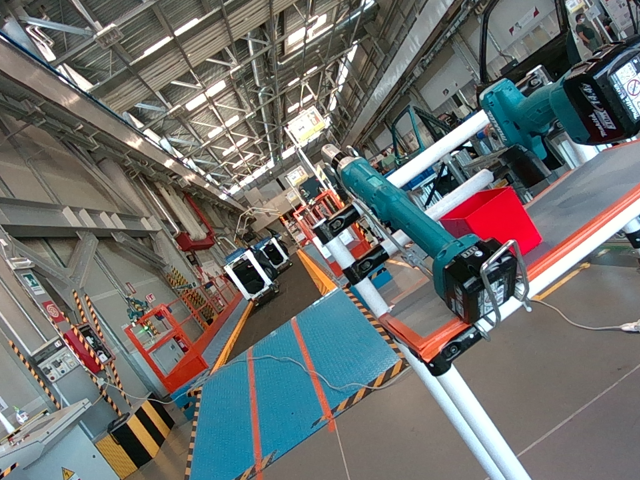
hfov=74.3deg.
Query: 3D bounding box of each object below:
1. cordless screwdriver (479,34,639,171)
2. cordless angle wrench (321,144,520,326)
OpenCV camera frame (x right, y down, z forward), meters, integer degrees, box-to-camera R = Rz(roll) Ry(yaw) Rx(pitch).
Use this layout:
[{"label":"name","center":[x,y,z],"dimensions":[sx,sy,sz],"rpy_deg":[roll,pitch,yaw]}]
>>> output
[{"label":"cordless screwdriver","center":[0.322,-0.157,0.560],"dimensions":[0.074,0.159,0.248],"rpy_deg":[-37,12,-3]},{"label":"cordless angle wrench","center":[0.105,-0.052,0.633],"dimensions":[0.074,0.098,0.422],"rpy_deg":[-31,45,-9]}]
